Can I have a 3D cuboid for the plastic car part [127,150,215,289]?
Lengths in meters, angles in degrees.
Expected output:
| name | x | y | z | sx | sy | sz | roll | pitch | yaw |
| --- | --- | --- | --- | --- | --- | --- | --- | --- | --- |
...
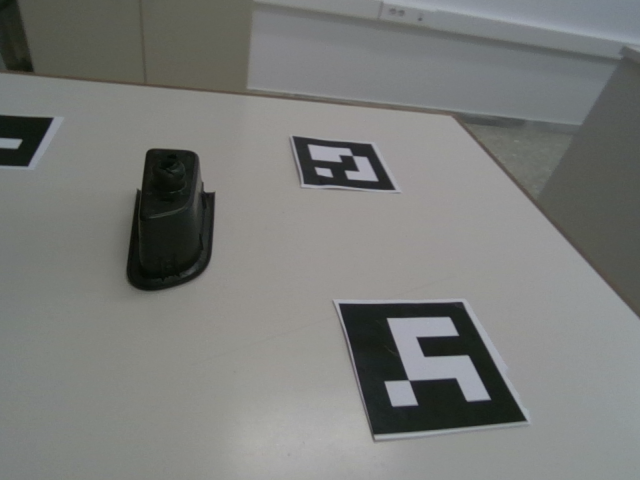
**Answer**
| name | x | y | z | sx | sy | sz | roll | pitch | yaw |
| --- | --- | --- | --- | --- | --- | --- | --- | --- | --- |
| plastic car part | -0.112 | -0.028 | 0.322 | 0.065 | 0.071 | 0.117 | 0 | 37 | -14 |
